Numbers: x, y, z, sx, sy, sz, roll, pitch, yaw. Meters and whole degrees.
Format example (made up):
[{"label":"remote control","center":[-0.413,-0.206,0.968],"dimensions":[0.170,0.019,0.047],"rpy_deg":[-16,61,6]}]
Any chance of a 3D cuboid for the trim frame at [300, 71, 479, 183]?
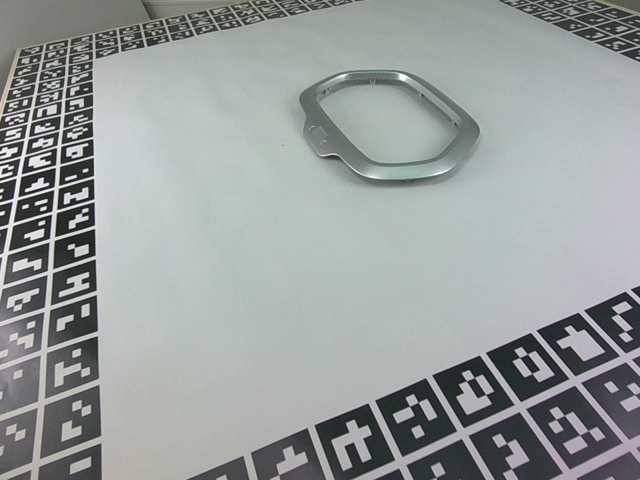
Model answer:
[{"label":"trim frame","center":[0.073,-0.147,0.513],"dimensions":[0.184,0.248,0.027],"rpy_deg":[-19,-39,-13]}]
